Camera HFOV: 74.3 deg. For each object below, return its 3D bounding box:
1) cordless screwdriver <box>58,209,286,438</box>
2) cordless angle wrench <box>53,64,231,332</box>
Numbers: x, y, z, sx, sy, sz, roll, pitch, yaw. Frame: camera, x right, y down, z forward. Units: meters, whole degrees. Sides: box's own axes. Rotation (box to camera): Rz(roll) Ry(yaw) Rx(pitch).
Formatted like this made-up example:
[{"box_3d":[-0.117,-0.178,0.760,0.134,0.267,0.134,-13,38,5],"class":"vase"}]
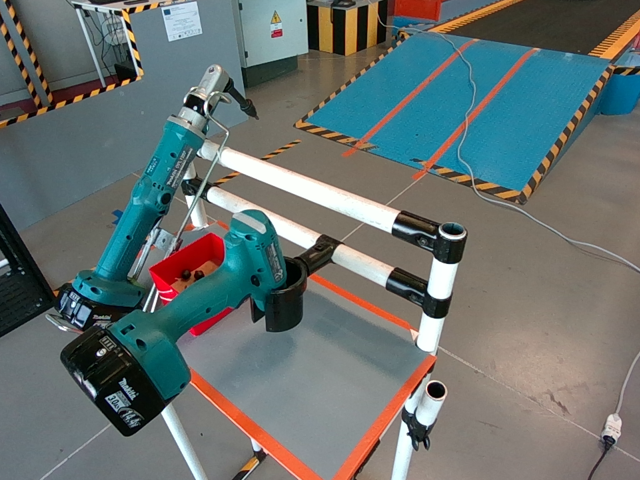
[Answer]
[{"box_3d":[-0.130,0.094,0.466,0.074,0.159,0.248,26,56,33],"class":"cordless screwdriver"},{"box_3d":[-0.240,-0.067,0.618,0.074,0.423,0.098,26,-1,26],"class":"cordless angle wrench"}]
